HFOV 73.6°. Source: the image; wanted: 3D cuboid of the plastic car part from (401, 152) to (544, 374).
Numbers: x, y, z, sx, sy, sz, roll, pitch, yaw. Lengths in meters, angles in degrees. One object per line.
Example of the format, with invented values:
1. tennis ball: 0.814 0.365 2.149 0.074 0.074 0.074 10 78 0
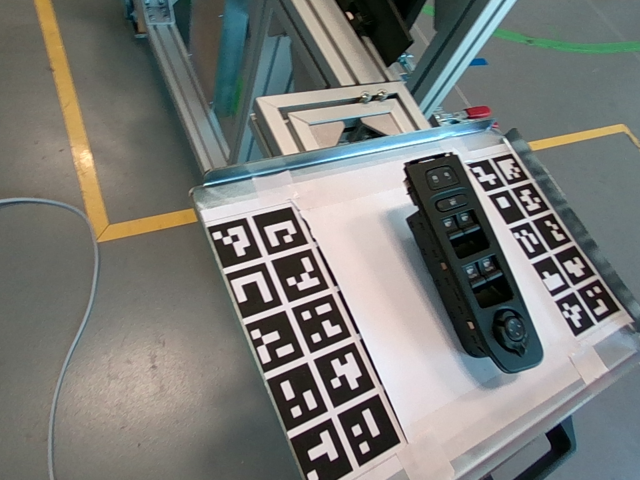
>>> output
1. plastic car part: 0.126 0.025 0.386 0.066 0.203 0.067 -14 -17 -34
